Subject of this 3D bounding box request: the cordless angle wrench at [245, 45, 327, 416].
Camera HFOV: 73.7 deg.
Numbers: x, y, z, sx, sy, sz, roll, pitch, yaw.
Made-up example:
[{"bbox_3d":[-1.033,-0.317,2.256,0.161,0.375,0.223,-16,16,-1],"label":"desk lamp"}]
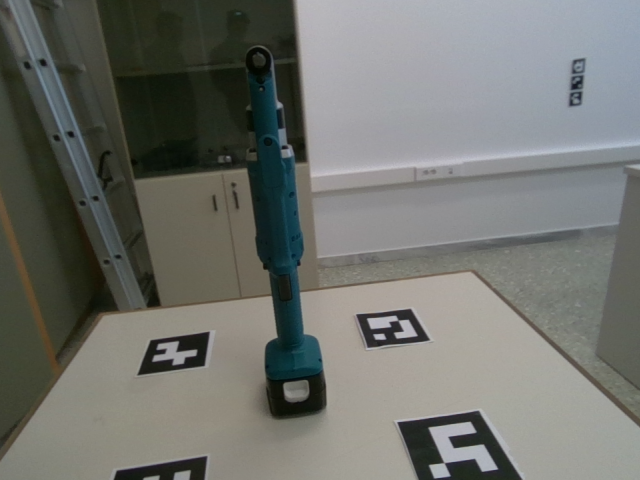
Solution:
[{"bbox_3d":[-0.046,0.006,0.495,0.074,0.422,0.098,-6,20,-4],"label":"cordless angle wrench"}]
